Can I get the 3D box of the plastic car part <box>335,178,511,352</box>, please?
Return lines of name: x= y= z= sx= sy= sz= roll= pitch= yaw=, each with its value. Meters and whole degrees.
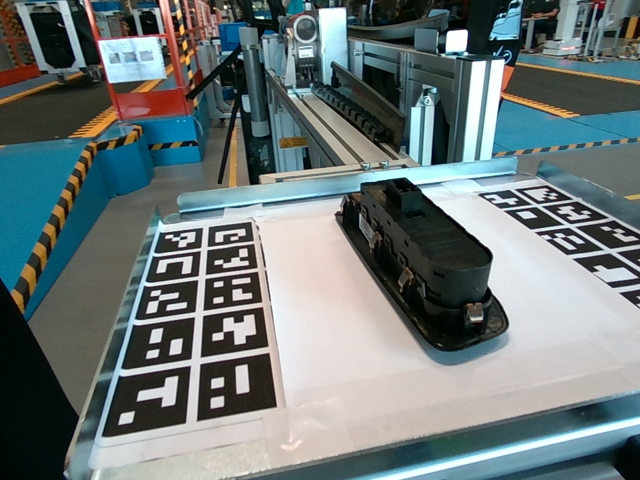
plastic car part: x=0.069 y=-0.003 z=0.315 sx=0.066 sy=0.067 sz=0.203 roll=-3 pitch=31 yaw=-13
